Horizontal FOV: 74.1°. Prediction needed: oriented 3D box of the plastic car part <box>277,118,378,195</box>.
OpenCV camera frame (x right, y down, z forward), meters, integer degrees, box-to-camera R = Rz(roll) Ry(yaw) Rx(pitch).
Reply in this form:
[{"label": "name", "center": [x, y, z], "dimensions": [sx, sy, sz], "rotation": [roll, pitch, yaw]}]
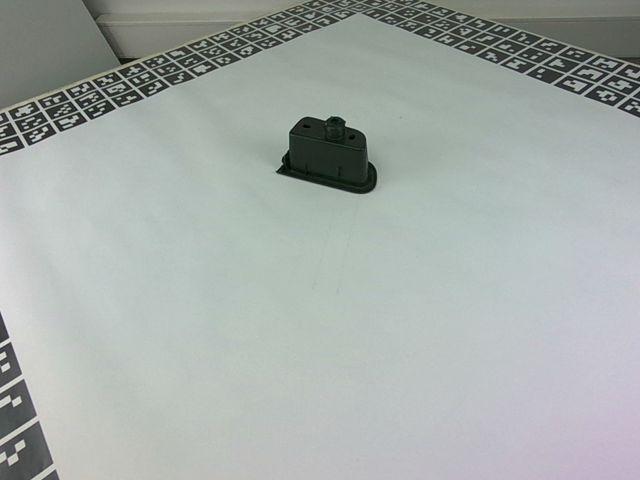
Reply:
[{"label": "plastic car part", "center": [0.012, -0.102, 0.477], "dimensions": [0.117, 0.065, 0.071], "rotation": [18, -37, 25]}]
